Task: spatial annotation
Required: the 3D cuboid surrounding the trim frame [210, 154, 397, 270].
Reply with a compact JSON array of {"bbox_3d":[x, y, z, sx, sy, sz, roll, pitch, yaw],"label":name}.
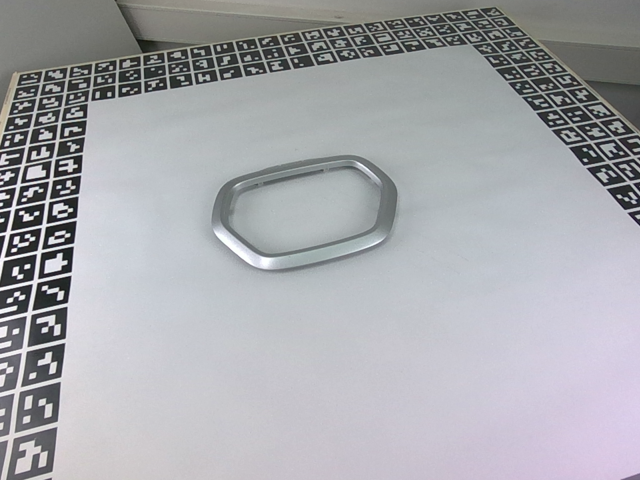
[{"bbox_3d":[-0.019,-0.046,0.554,0.248,0.184,0.027,-16,-35,-9],"label":"trim frame"}]
